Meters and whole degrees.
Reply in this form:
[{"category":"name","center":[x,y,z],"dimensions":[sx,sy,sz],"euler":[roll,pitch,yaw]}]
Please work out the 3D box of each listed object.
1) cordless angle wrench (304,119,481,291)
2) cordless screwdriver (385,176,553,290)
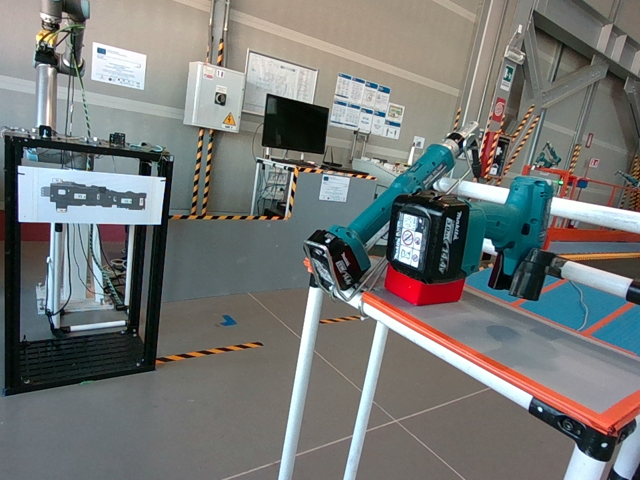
[{"category":"cordless angle wrench","center":[0.153,-0.088,0.752],"dimensions":[0.422,0.098,0.074],"euler":[-43,43,-17]},{"category":"cordless screwdriver","center":[0.197,0.006,0.527],"dimensions":[0.248,0.159,0.074],"euler":[-9,18,-32]}]
